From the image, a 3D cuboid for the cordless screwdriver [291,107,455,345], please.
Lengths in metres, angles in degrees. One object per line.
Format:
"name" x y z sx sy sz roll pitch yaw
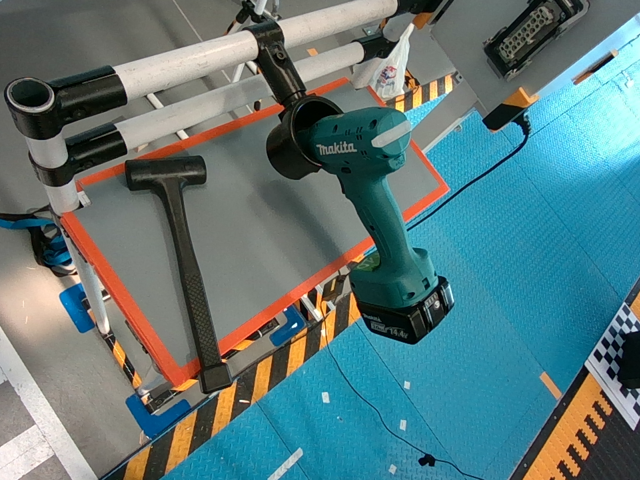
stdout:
"cordless screwdriver" 0.049 -0.015 0.464 0.074 0.249 0.159 -33 25 -29
